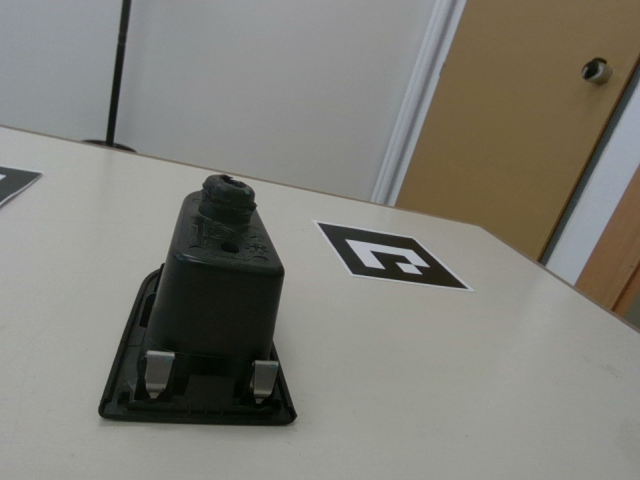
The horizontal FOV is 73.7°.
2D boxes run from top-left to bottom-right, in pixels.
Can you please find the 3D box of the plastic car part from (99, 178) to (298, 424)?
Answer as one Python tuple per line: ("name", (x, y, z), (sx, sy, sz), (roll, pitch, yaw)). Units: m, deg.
("plastic car part", (-0.045, 0.011, 0.186), (0.065, 0.071, 0.117), (9, 23, -18))
